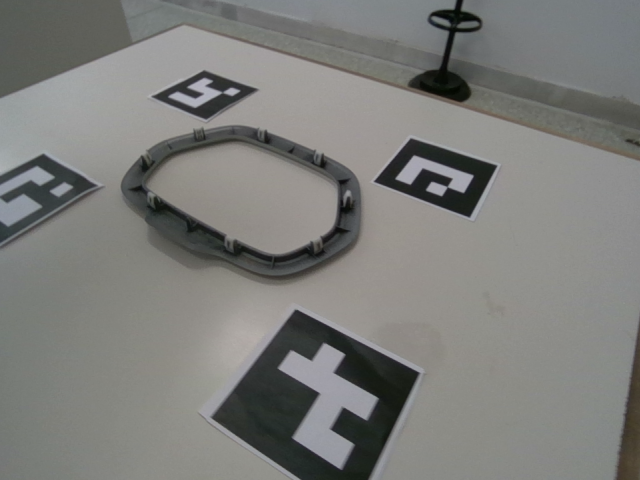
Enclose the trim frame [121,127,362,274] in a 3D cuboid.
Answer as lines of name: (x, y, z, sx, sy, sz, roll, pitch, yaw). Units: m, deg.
trim frame: (-0.075, -0.053, 0.412, 0.250, 0.027, 0.183, 28, 52, 23)
